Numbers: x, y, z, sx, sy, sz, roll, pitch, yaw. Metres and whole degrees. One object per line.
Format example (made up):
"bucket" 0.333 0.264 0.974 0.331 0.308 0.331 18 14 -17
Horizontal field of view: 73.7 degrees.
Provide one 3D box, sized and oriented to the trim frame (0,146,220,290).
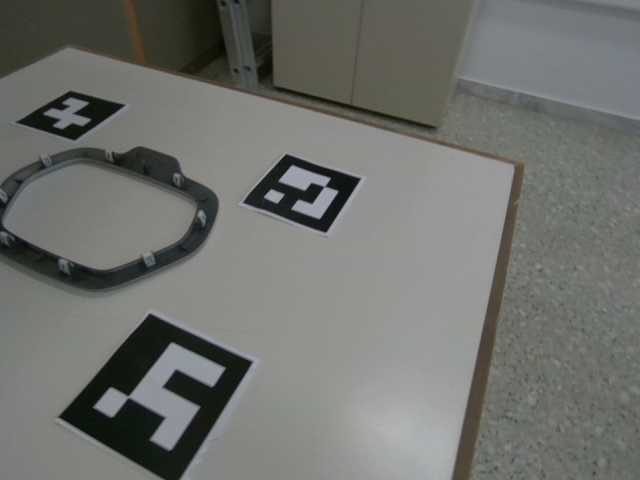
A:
"trim frame" -0.224 -0.037 0.436 0.250 0.027 0.183 19 47 18
